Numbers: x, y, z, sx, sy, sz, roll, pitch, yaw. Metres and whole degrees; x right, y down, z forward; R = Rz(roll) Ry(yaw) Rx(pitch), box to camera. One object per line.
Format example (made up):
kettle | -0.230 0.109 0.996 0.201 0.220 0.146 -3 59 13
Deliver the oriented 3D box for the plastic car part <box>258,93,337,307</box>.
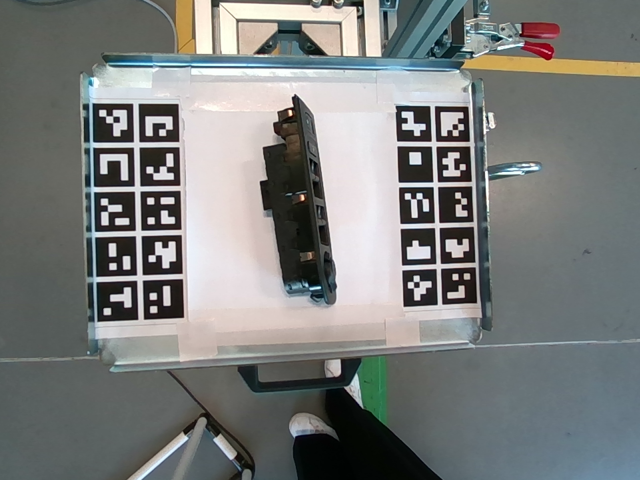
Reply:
plastic car part | -0.022 -0.031 0.417 0.067 0.203 0.066 -13 -4 3
